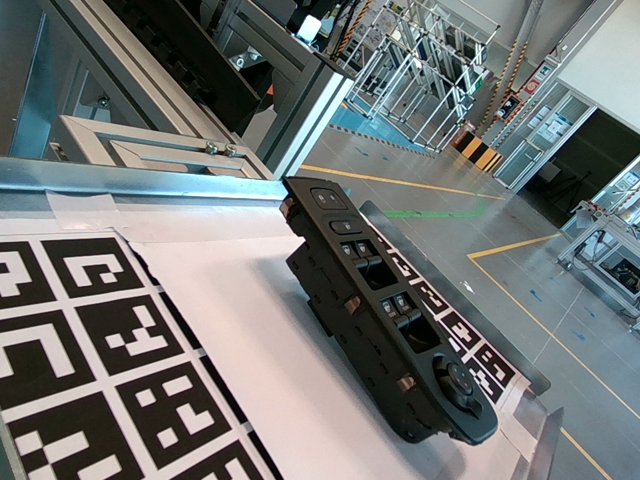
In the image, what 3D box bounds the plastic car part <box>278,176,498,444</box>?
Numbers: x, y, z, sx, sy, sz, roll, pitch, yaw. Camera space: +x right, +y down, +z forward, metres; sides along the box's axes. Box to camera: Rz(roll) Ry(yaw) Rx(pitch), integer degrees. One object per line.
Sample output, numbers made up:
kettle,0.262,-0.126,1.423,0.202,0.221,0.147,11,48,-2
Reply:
plastic car part,0.032,0.048,0.285,0.067,0.203,0.066,-46,-21,20
